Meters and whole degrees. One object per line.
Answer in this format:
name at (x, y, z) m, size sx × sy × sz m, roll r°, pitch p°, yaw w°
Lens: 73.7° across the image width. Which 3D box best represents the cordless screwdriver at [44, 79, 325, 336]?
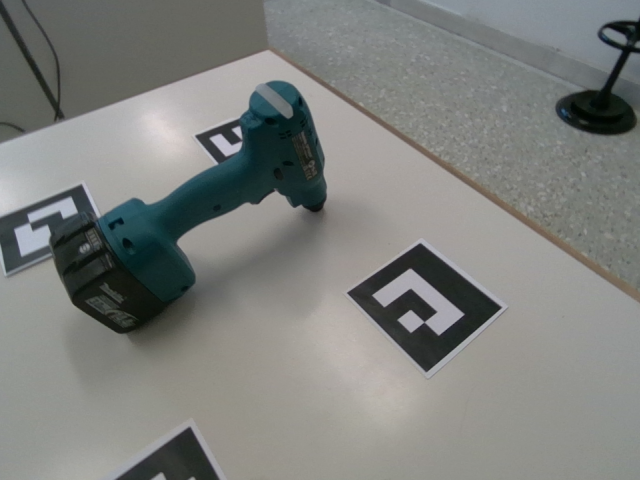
cordless screwdriver at (-0.099, -0.017, 0.396) m, size 0.248 × 0.075 × 0.158 m, roll -38°, pitch -31°, yaw -9°
